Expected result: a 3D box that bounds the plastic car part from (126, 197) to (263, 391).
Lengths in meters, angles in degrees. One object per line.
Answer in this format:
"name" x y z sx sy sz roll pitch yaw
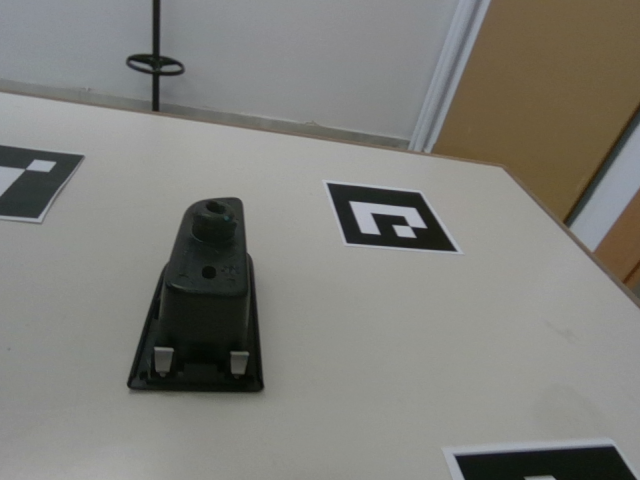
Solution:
"plastic car part" -0.063 0.016 0.240 0.065 0.071 0.117 6 39 -13
